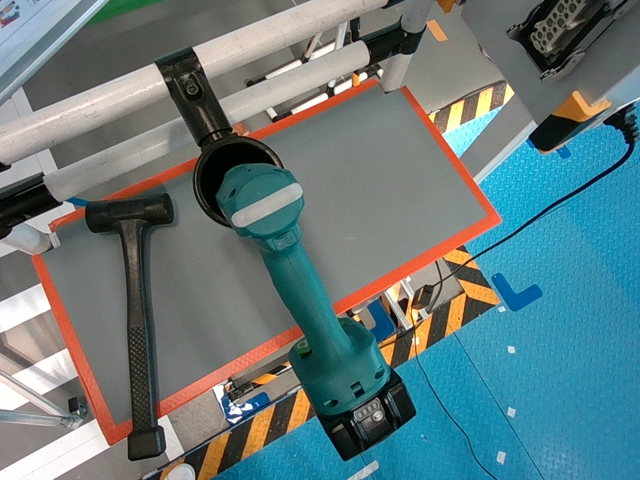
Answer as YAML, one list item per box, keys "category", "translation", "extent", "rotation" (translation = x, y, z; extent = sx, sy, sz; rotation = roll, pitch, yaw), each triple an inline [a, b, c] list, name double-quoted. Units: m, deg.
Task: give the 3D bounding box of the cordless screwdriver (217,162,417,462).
- category: "cordless screwdriver"
  translation: [-0.015, 0.049, 0.367]
  extent: [0.074, 0.249, 0.159]
  rotation: [-28, 17, -10]
